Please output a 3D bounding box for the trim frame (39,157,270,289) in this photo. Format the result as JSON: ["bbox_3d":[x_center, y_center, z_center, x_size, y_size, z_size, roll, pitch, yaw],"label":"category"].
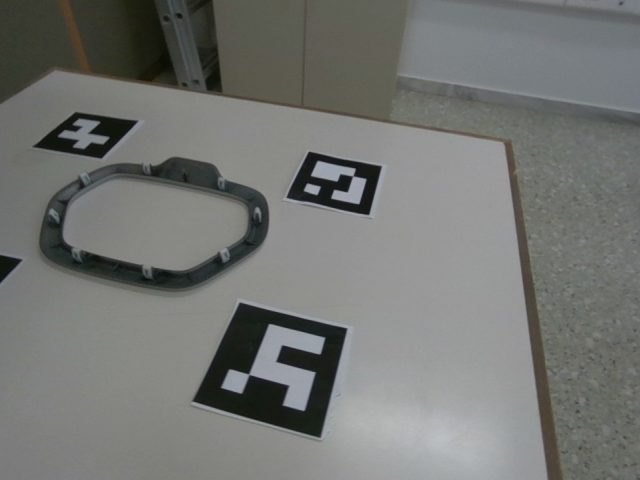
[{"bbox_3d":[-0.175,-0.029,0.457,0.249,0.027,0.183,11,45,11],"label":"trim frame"}]
